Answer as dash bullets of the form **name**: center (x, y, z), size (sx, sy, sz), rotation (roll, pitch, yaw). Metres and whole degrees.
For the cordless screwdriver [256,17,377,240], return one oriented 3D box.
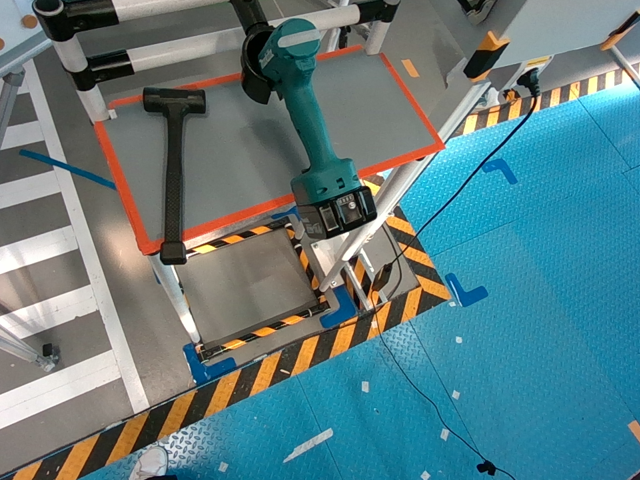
- **cordless screwdriver**: center (-0.020, -0.129, 0.535), size (0.074, 0.249, 0.159), rotation (-23, 16, -18)
